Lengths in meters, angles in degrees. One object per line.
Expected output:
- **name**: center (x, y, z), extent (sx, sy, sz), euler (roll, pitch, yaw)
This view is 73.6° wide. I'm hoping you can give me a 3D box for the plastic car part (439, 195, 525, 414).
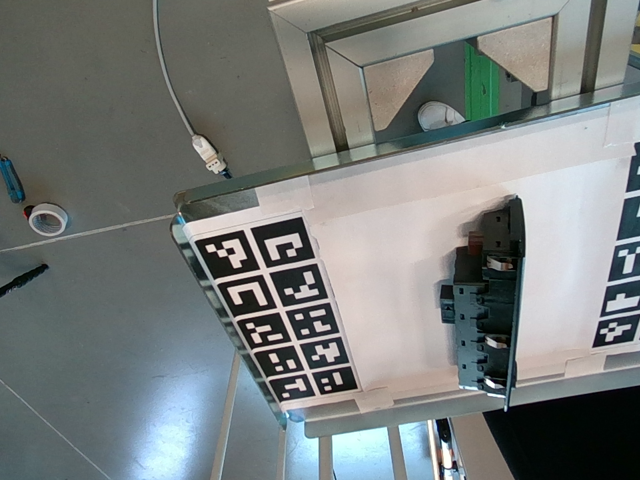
- **plastic car part**: center (0.133, 0.068, 0.345), extent (0.067, 0.203, 0.066), euler (-7, 36, 19)
